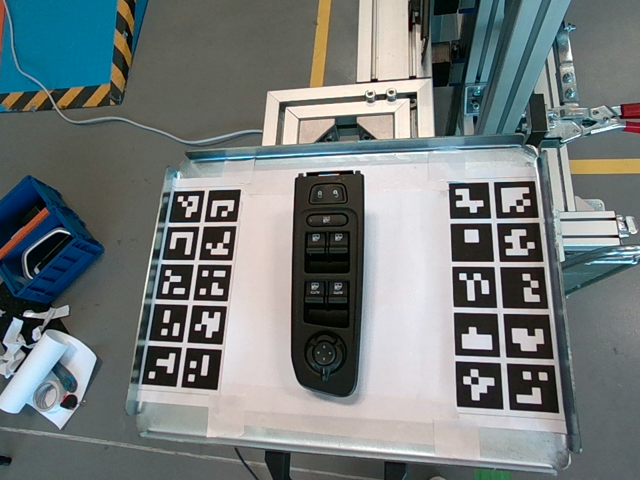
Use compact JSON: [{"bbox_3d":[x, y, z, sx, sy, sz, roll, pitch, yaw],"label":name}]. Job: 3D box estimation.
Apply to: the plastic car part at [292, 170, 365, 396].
[{"bbox_3d":[0.008,0.039,0.407,0.066,0.202,0.067,1,-14,4],"label":"plastic car part"}]
